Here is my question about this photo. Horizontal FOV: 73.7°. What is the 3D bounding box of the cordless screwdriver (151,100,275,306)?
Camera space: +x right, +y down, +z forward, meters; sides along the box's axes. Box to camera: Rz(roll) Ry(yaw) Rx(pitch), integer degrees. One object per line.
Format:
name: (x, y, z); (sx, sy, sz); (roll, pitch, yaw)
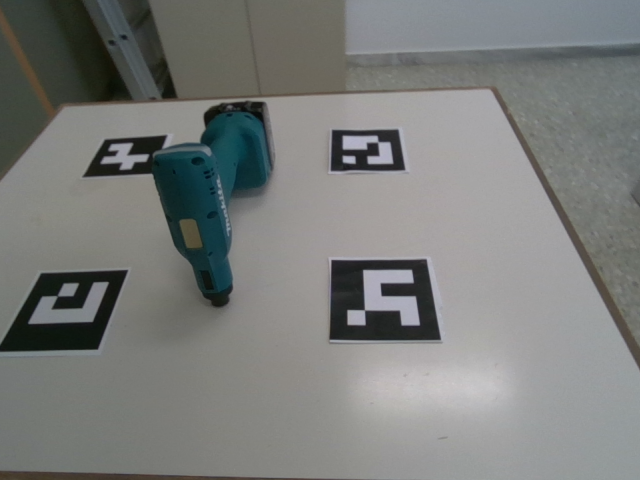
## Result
cordless screwdriver: (-0.102, -0.057, 0.473); (0.074, 0.159, 0.248); (-4, 30, 5)
